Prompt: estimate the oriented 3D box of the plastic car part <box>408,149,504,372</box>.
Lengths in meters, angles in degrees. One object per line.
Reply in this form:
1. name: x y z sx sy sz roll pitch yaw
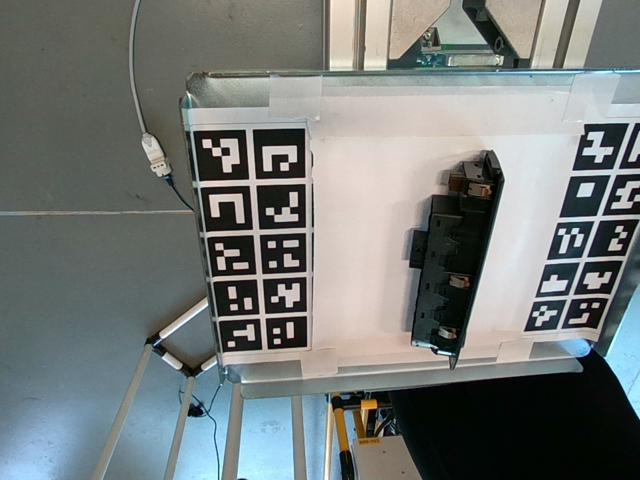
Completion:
1. plastic car part: 0.110 0.029 0.370 0.067 0.203 0.066 1 27 7
